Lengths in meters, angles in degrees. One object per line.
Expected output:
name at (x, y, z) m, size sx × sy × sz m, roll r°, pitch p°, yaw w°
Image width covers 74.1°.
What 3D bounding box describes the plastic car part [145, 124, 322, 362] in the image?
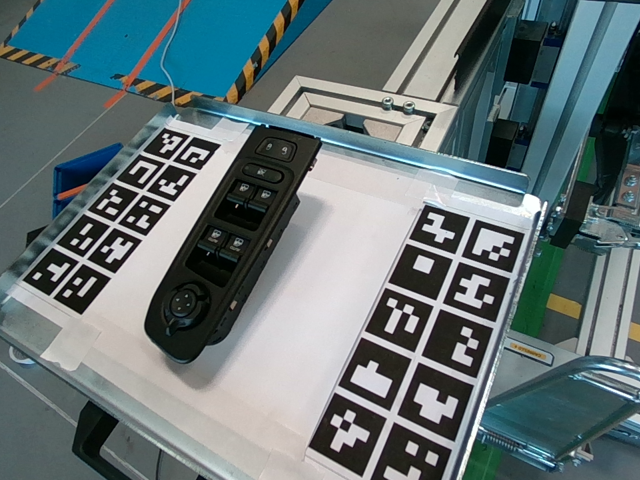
plastic car part at (-0.067, 0.002, 0.347) m, size 0.066 × 0.202 × 0.067 m, roll 22°, pitch -23°, yaw 15°
